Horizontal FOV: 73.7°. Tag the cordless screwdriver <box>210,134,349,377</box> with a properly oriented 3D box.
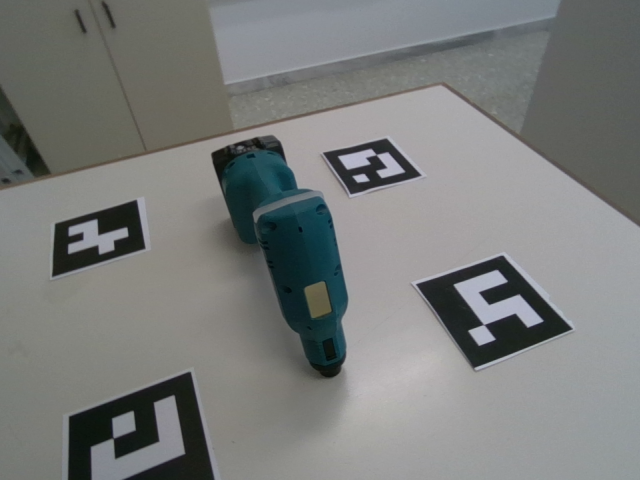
[{"bbox_3d":[-0.037,-0.002,0.401,0.074,0.159,0.250,-19,30,-10],"label":"cordless screwdriver"}]
